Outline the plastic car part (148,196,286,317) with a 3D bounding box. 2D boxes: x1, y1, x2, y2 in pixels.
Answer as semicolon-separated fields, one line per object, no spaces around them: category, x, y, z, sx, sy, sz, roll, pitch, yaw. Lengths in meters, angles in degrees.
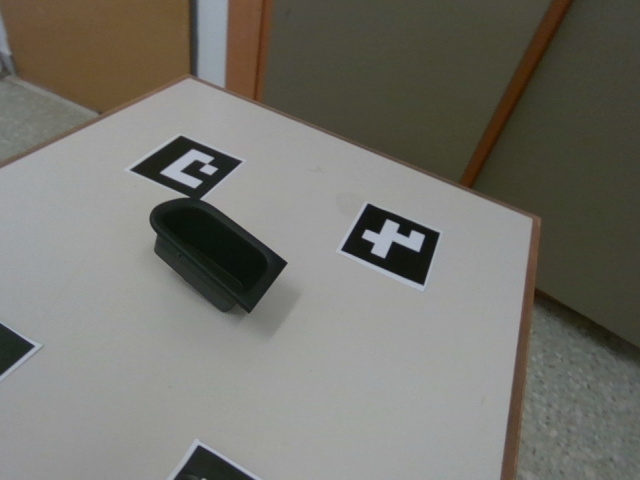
plastic car part;-0.102;0.017;0.392;0.065;0.116;0.071;-53;3;-38
